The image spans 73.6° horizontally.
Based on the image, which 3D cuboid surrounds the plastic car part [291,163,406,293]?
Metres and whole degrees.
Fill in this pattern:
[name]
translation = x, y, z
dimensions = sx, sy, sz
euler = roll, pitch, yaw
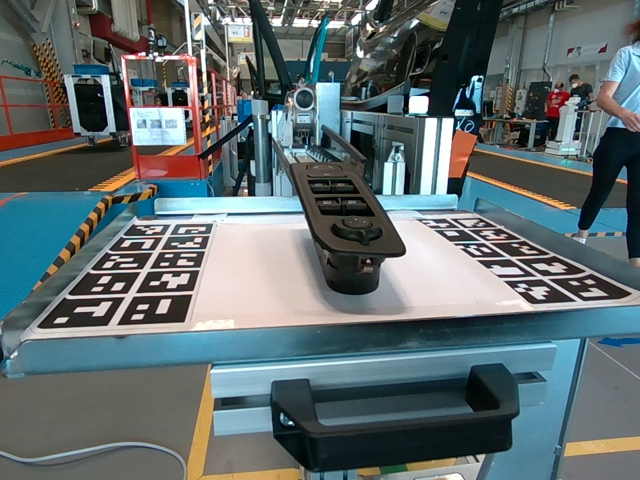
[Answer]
[plastic car part]
translation = 0.014, -0.017, 0.373
dimensions = 0.066, 0.067, 0.203
euler = 5, 21, -12
